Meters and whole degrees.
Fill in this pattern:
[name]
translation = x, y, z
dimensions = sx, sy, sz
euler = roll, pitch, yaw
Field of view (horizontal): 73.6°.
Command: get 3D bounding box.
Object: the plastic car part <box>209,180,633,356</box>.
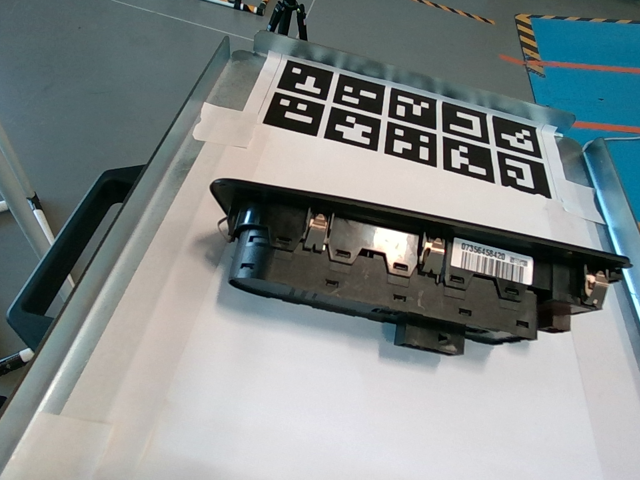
[plastic car part]
translation = 0.040, 0.019, 0.219
dimensions = 0.203, 0.067, 0.066
euler = 16, -12, -3
